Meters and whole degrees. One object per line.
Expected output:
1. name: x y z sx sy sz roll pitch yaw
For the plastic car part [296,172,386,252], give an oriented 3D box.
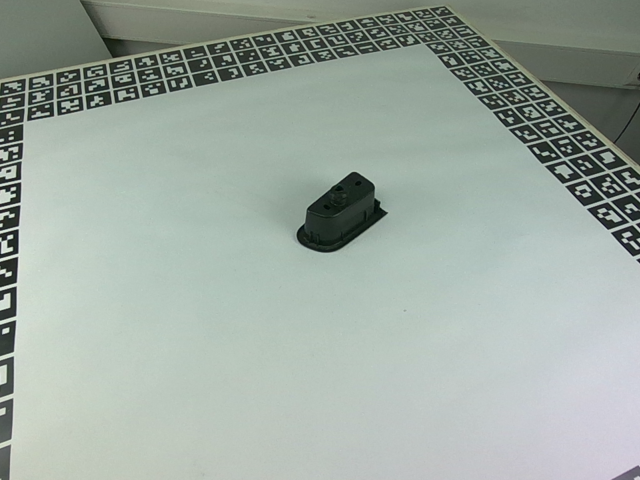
1. plastic car part: 0.025 -0.041 0.527 0.066 0.071 0.116 40 58 23
